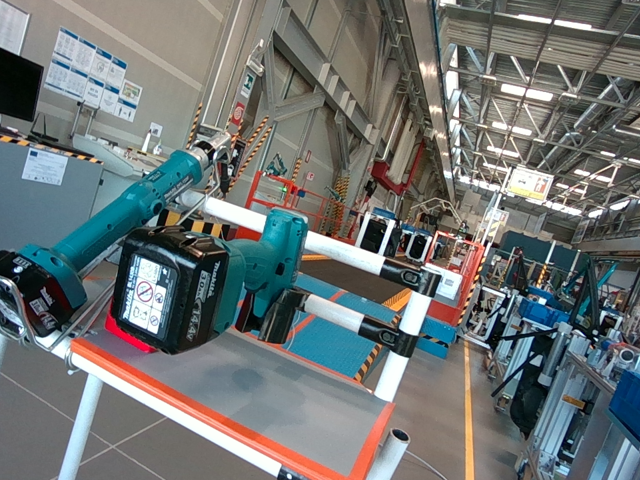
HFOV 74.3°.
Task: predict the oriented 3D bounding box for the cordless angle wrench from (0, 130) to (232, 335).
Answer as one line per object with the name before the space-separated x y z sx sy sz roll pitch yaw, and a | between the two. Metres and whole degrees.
cordless angle wrench | -0.259 -0.054 0.616 0.074 0.098 0.421 26 50 13

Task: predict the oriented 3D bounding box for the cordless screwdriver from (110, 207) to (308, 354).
cordless screwdriver | -0.093 0.051 0.444 0.074 0.159 0.248 18 13 20
